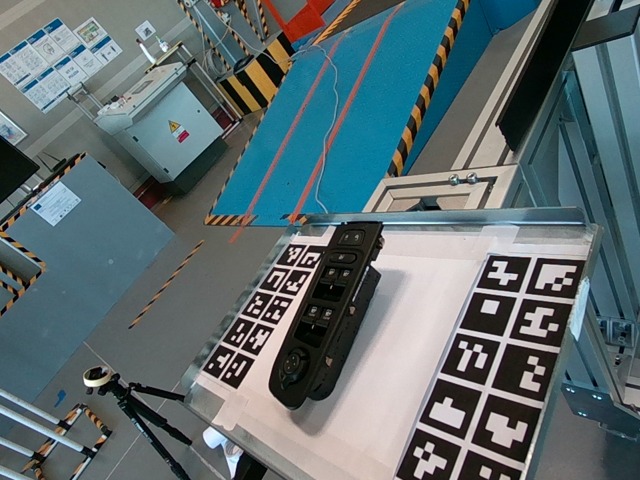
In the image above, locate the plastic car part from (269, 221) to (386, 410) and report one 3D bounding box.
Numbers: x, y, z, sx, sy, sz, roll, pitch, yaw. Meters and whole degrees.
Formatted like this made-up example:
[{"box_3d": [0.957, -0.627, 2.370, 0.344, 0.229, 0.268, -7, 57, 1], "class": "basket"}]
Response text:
[{"box_3d": [0.013, 0.077, 0.440, 0.067, 0.202, 0.067, 7, -32, 41], "class": "plastic car part"}]
